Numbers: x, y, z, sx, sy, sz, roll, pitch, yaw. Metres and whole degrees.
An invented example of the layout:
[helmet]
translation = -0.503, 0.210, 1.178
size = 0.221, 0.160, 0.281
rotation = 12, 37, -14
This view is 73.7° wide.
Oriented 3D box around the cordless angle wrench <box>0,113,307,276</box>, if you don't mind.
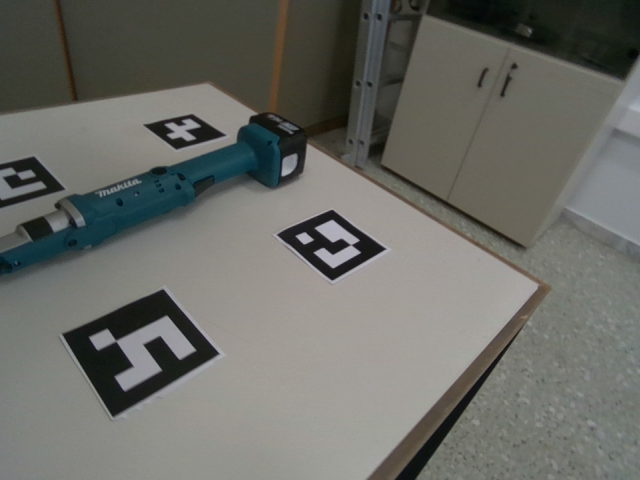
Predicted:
[cordless angle wrench]
translation = -0.191, -0.060, 0.522
size = 0.099, 0.074, 0.419
rotation = 35, 47, 28
